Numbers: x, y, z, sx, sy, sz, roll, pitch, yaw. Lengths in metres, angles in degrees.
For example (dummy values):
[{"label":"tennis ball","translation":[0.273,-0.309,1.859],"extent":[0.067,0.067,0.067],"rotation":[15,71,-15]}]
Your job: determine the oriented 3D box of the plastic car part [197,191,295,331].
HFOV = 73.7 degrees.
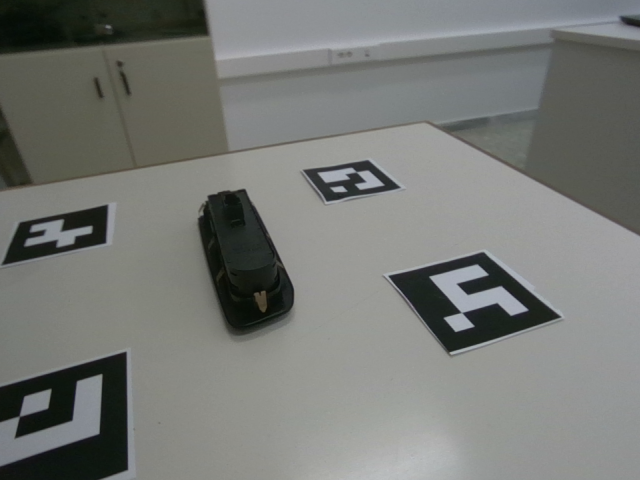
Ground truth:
[{"label":"plastic car part","translation":[-0.072,0.000,0.394],"extent":[0.066,0.067,0.204],"rotation":[-7,34,-19]}]
